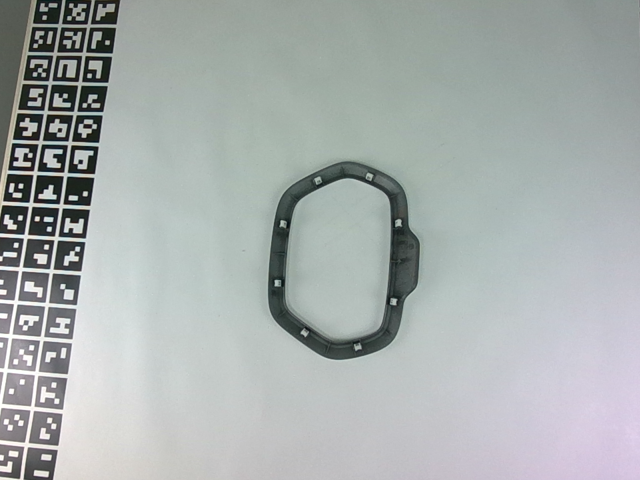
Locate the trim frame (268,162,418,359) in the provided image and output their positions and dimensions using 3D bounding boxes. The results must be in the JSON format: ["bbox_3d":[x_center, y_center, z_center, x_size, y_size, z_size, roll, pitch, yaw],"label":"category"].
[{"bbox_3d":[0.027,0.021,0.528,0.184,0.248,0.027,5,-9,5],"label":"trim frame"}]
